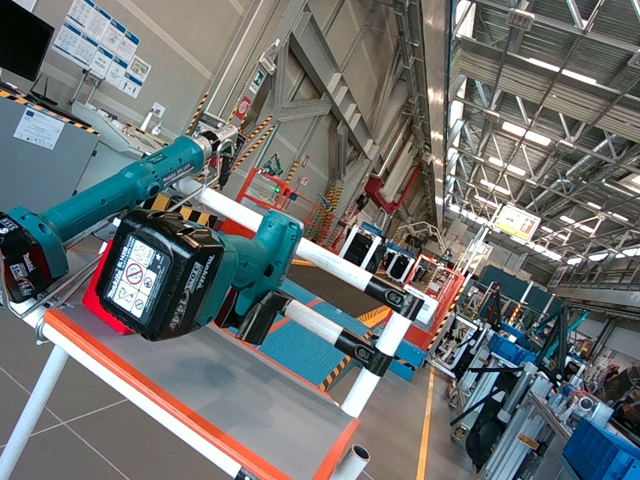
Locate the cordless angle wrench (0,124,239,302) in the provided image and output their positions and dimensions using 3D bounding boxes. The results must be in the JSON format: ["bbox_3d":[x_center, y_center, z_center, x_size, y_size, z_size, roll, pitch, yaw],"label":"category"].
[{"bbox_3d":[-0.259,-0.081,0.606,0.074,0.098,0.421,34,48,12],"label":"cordless angle wrench"}]

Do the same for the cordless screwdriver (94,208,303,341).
[{"bbox_3d":[-0.106,0.045,0.441,0.074,0.159,0.248,27,12,18],"label":"cordless screwdriver"}]
